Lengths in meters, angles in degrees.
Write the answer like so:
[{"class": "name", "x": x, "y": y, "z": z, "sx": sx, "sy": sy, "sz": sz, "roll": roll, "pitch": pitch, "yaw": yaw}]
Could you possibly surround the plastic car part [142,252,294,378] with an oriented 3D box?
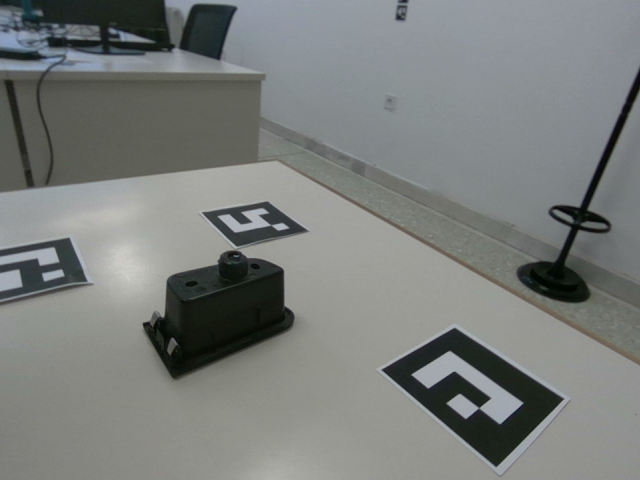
[{"class": "plastic car part", "x": -0.077, "y": 0.046, "z": 0.342, "sx": 0.115, "sy": 0.071, "sz": 0.066, "roll": -19, "pitch": 37, "yaw": -32}]
